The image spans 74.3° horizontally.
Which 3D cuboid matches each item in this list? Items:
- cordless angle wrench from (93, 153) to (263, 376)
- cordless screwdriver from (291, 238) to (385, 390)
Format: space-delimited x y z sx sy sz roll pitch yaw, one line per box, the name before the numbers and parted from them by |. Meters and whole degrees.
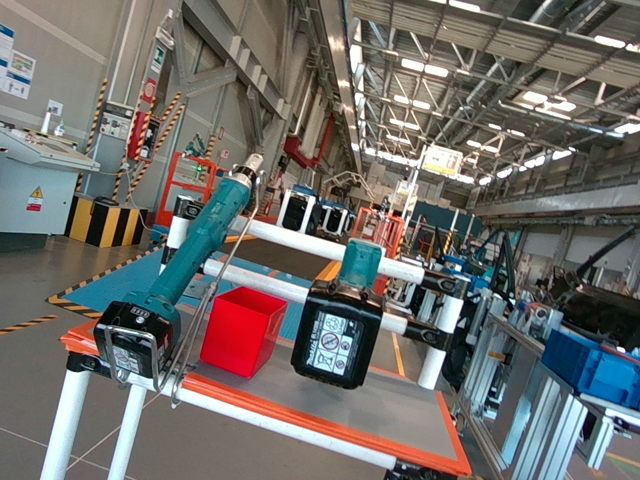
cordless angle wrench | -0.171 -0.007 0.634 0.074 0.421 0.098 21 -42 1
cordless screwdriver | 0.029 0.097 0.515 0.074 0.159 0.248 15 14 7
